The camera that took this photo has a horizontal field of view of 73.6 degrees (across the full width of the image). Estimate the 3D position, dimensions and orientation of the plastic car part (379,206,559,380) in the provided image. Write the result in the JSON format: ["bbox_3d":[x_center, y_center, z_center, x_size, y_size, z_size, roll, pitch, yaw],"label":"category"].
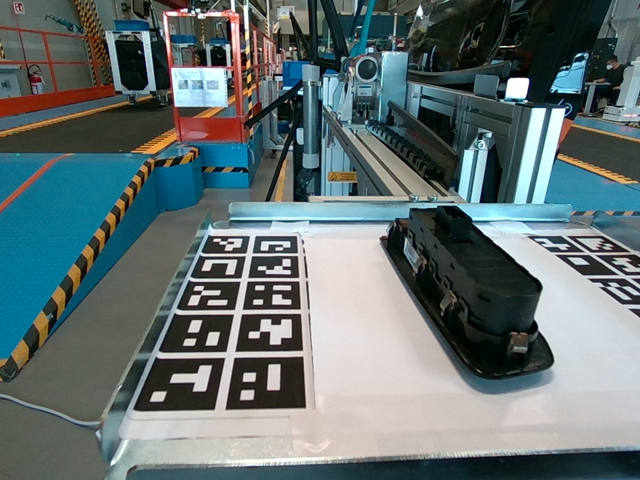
[{"bbox_3d":[0.101,0.017,0.310,0.066,0.067,0.203,5,26,-8],"label":"plastic car part"}]
